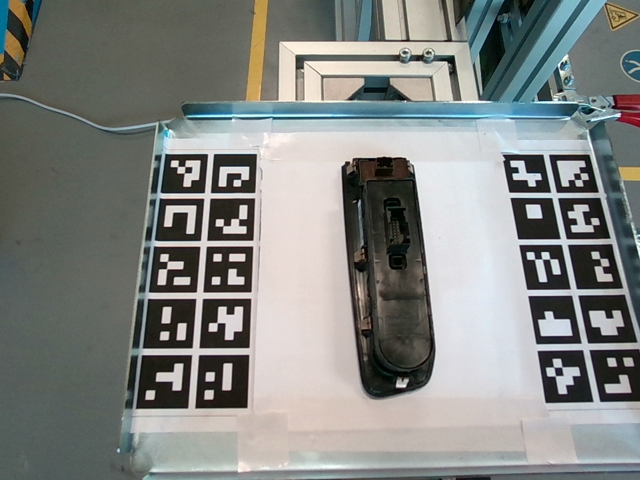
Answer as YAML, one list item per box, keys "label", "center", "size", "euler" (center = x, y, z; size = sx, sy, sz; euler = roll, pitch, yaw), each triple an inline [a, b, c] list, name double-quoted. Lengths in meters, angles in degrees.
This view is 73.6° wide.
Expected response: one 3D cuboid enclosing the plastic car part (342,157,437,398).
- label: "plastic car part"
  center: [0.060, 0.018, 0.337]
  size: [0.066, 0.202, 0.067]
  euler: [0, -16, -8]
